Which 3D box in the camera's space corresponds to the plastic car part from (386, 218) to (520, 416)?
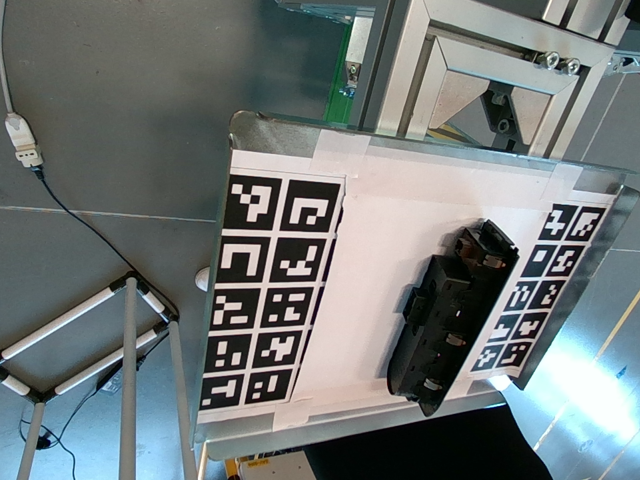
[{"bbox_3d":[0.108,0.081,0.394,0.067,0.203,0.066,3,28,-15],"label":"plastic car part"}]
